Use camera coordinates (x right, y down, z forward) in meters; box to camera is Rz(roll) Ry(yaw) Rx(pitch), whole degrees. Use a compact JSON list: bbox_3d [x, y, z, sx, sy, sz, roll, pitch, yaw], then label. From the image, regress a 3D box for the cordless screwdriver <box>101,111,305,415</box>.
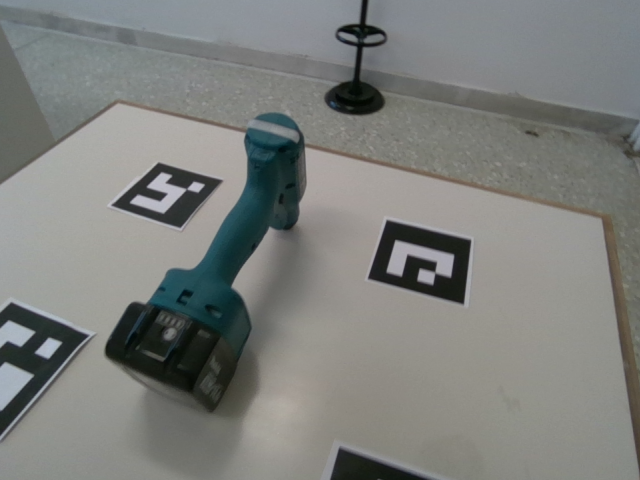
[{"bbox_3d":[-0.076,0.023,0.389,0.074,0.248,0.159,18,-27,10],"label":"cordless screwdriver"}]
